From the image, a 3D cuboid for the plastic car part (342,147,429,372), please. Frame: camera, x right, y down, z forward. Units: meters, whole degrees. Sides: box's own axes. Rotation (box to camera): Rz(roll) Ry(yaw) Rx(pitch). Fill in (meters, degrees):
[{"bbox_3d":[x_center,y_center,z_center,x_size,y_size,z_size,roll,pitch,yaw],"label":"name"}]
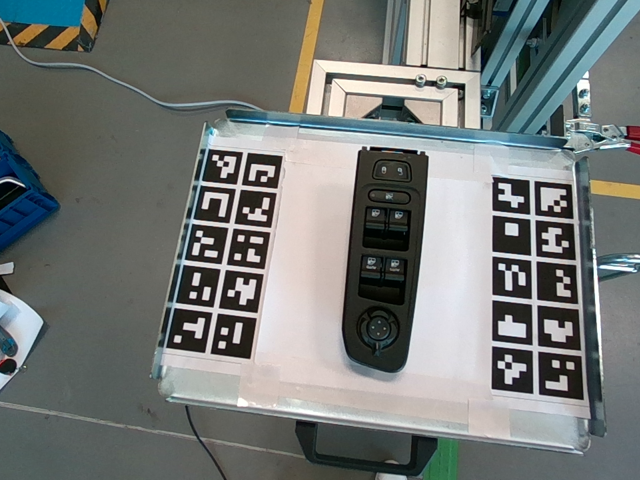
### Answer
[{"bbox_3d":[0.056,0.018,0.406,0.066,0.202,0.067,7,-13,-5],"label":"plastic car part"}]
